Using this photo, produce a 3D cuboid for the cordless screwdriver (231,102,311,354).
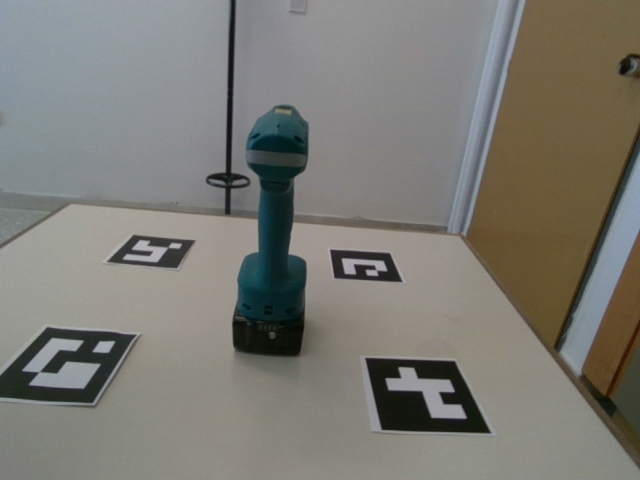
[{"bbox_3d":[-0.044,-0.014,0.449,0.074,0.249,0.159,5,28,-2],"label":"cordless screwdriver"}]
